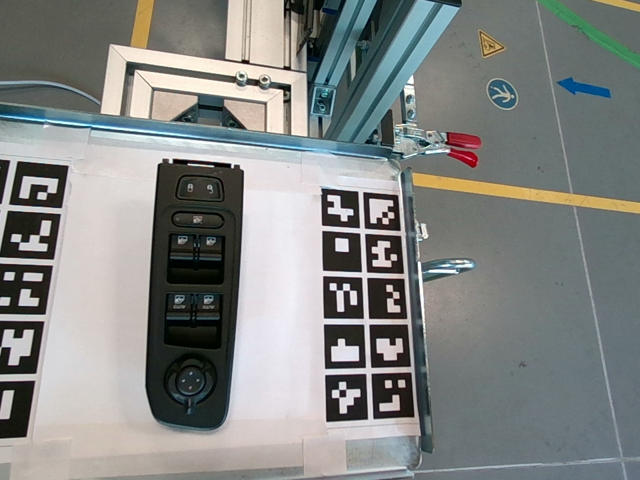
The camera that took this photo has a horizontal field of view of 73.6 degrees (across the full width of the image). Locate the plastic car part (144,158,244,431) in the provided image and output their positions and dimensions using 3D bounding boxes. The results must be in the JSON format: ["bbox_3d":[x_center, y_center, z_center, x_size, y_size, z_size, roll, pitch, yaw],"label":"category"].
[{"bbox_3d":[-0.101,0.042,0.339,0.066,0.202,0.067,4,-13,-22],"label":"plastic car part"}]
